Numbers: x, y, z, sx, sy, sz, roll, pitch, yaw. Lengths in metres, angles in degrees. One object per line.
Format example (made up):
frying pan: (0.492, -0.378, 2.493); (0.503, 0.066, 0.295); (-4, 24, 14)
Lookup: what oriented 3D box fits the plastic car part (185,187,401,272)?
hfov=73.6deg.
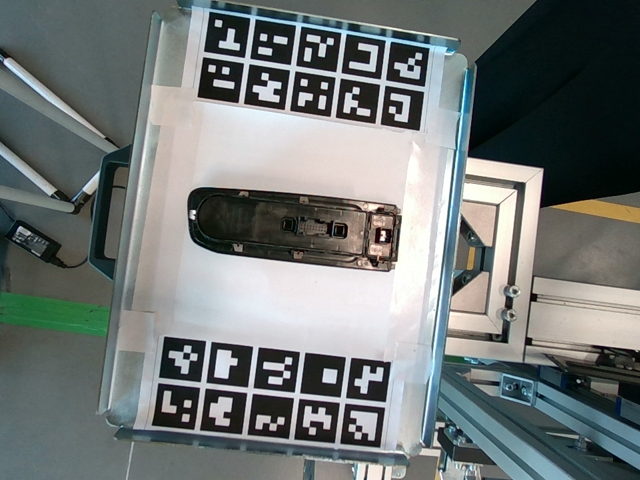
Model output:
plastic car part: (-0.025, -0.010, 0.385); (0.203, 0.066, 0.067); (6, 4, -1)
